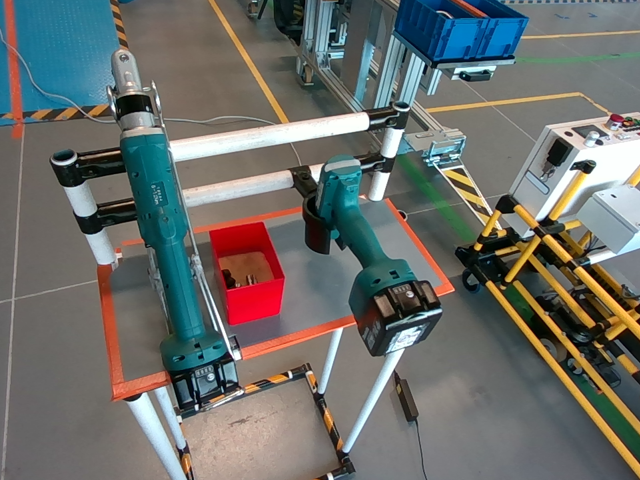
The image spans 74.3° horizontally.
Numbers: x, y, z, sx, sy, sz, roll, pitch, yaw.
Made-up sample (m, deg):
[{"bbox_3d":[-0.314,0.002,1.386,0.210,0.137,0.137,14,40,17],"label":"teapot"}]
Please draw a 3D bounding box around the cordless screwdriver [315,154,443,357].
[{"bbox_3d":[0.054,0.027,0.555,0.074,0.248,0.160,-13,-30,-17],"label":"cordless screwdriver"}]

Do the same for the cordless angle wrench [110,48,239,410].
[{"bbox_3d":[-0.189,-0.017,0.510,0.074,0.423,0.098,-14,4,-25],"label":"cordless angle wrench"}]
